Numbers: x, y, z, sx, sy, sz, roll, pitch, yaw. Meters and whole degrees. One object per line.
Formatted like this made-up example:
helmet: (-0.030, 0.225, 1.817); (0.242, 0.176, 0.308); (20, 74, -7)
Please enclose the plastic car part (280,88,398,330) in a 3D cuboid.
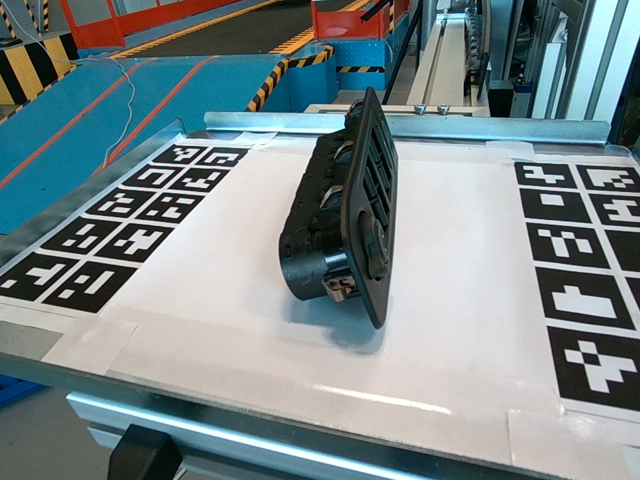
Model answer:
plastic car part: (0.016, -0.030, 0.265); (0.067, 0.066, 0.202); (-12, 32, 13)
